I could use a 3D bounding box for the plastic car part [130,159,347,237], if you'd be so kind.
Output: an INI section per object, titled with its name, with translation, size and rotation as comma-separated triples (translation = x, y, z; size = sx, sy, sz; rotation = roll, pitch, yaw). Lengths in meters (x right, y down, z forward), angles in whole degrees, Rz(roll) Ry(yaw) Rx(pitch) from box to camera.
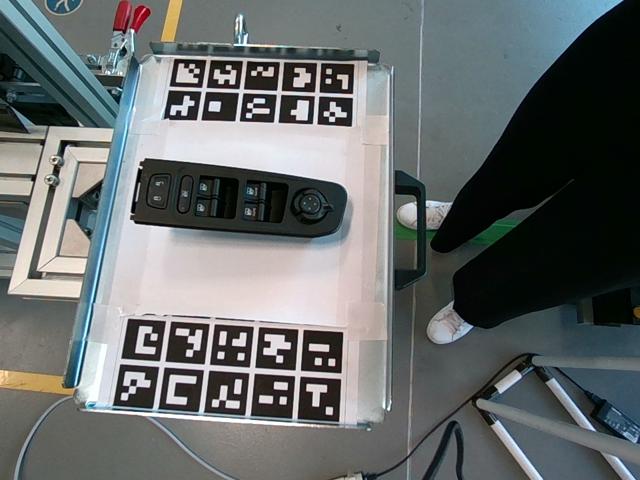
[plastic car part]
translation = -0.075, -0.031, 0.429
size = 0.203, 0.066, 0.067
rotation = 3, -23, -1
